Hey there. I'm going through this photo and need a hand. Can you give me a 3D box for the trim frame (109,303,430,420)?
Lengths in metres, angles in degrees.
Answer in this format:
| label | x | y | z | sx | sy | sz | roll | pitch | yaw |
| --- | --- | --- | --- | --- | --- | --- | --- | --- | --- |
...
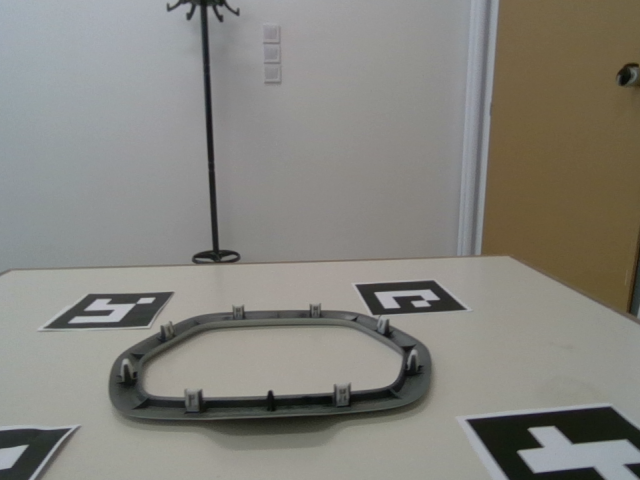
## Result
| label | x | y | z | sx | sy | sz | roll | pitch | yaw |
| --- | --- | --- | --- | --- | --- | --- | --- | --- | --- |
| trim frame | -0.037 | 0.090 | 0.343 | 0.248 | 0.027 | 0.184 | 0 | 14 | -2 |
